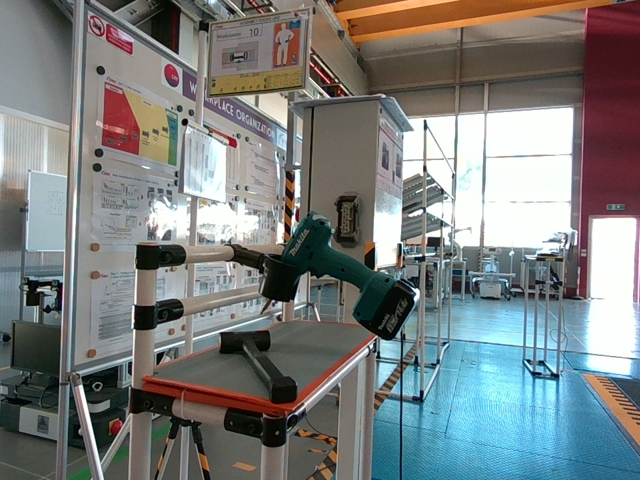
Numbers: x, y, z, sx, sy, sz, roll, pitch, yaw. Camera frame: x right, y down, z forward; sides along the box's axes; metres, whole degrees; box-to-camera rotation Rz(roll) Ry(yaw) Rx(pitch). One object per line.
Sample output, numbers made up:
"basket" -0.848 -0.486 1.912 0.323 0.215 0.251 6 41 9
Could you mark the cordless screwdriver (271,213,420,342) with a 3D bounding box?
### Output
"cordless screwdriver" 0.035 0.082 0.731 0.248 0.159 0.074 36 13 17
